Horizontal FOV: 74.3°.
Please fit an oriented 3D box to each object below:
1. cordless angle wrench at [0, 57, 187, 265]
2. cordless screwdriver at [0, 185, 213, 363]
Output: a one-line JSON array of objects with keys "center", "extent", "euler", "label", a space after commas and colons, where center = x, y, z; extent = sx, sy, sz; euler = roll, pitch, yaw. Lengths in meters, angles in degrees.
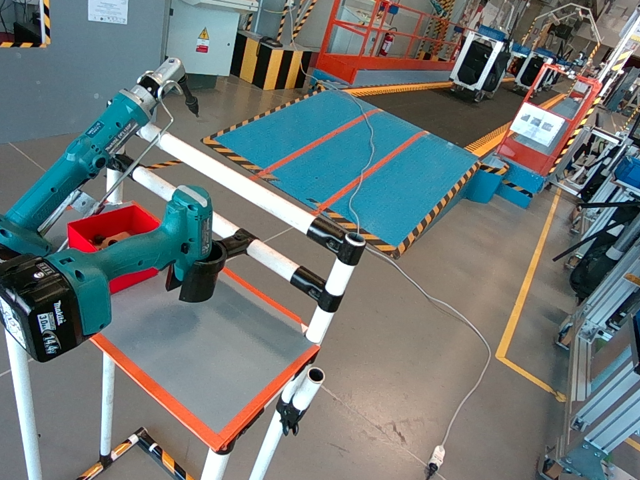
[{"center": [-0.348, -0.126, 0.637], "extent": [0.074, 0.422, 0.098], "euler": [33, -15, 14], "label": "cordless angle wrench"}, {"center": [-0.230, 0.045, 0.505], "extent": [0.074, 0.160, 0.248], "euler": [32, 42, 21], "label": "cordless screwdriver"}]
